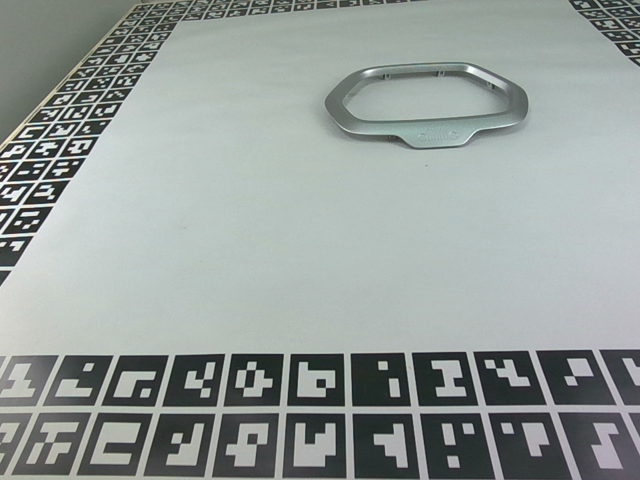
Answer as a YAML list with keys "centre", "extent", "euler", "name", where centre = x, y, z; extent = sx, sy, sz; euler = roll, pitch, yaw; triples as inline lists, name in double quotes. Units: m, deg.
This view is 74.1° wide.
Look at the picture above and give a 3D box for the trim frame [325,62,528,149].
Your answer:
- centre: [0.129, -0.175, 0.531]
  extent: [0.249, 0.183, 0.027]
  euler: [-3, -44, 2]
  name: "trim frame"
